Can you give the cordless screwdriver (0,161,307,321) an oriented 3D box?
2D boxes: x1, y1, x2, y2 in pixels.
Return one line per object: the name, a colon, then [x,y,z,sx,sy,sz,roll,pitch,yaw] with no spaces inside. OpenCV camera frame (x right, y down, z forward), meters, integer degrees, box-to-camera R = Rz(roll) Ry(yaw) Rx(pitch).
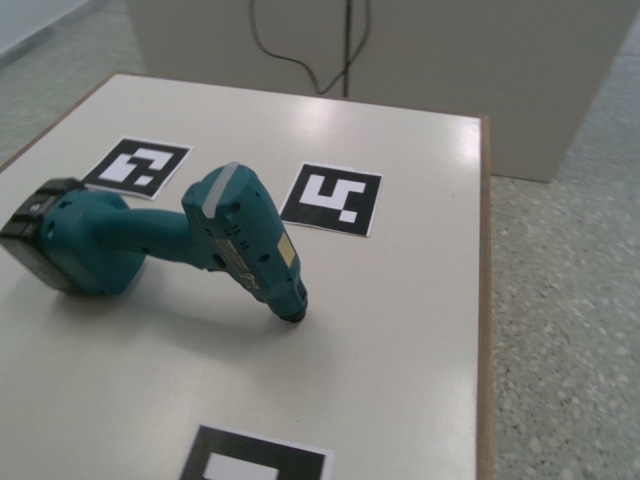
cordless screwdriver: [-0.136,0.014,0.372,0.251,0.074,0.158,0,-41,22]
